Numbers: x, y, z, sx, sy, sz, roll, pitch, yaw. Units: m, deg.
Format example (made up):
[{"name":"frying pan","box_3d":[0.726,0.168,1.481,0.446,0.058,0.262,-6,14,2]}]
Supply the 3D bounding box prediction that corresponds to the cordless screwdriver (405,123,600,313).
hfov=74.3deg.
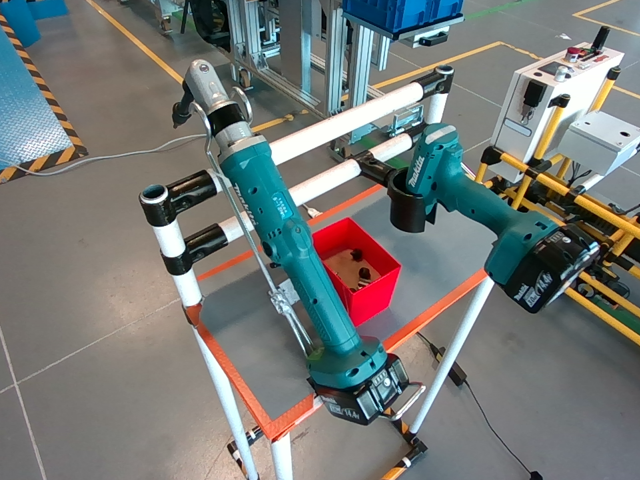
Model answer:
[{"name":"cordless screwdriver","box_3d":[0.201,-0.019,0.542,0.074,0.248,0.160,-27,-30,-23]}]

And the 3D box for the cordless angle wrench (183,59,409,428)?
[{"name":"cordless angle wrench","box_3d":[-0.038,0.000,0.465,0.074,0.423,0.098,-31,7,-34]}]
